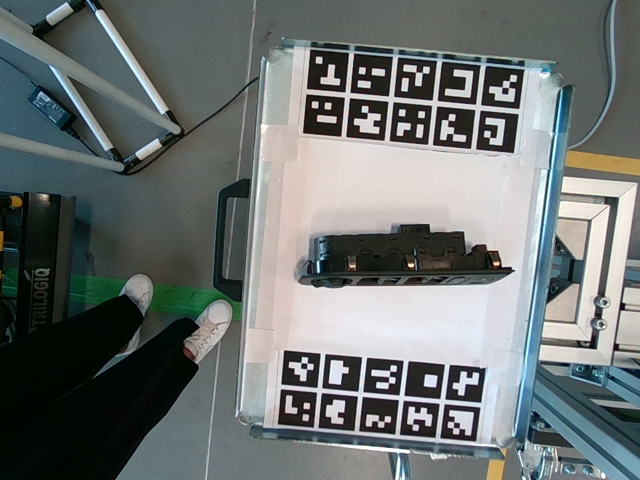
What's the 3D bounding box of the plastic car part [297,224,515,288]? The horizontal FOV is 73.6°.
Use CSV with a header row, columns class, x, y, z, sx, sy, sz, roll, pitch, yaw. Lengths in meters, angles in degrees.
class,x,y,z,sx,sy,sz,roll,pitch,yaw
plastic car part,0.077,0.018,0.424,0.203,0.067,0.066,-5,-7,-1
